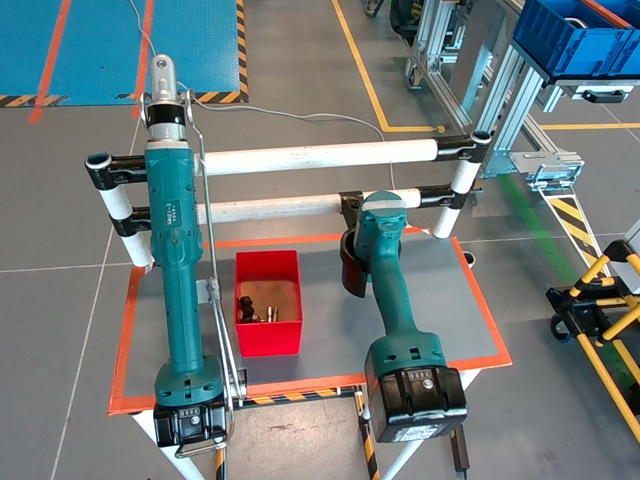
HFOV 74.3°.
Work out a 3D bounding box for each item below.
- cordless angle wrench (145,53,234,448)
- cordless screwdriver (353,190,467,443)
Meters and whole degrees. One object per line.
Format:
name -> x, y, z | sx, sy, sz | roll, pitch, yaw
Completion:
cordless angle wrench -> -0.155, 0.006, 0.473 | 0.074, 0.423, 0.098 | -5, 2, -5
cordless screwdriver -> 0.077, 0.087, 0.470 | 0.074, 0.248, 0.160 | -4, -32, -5
